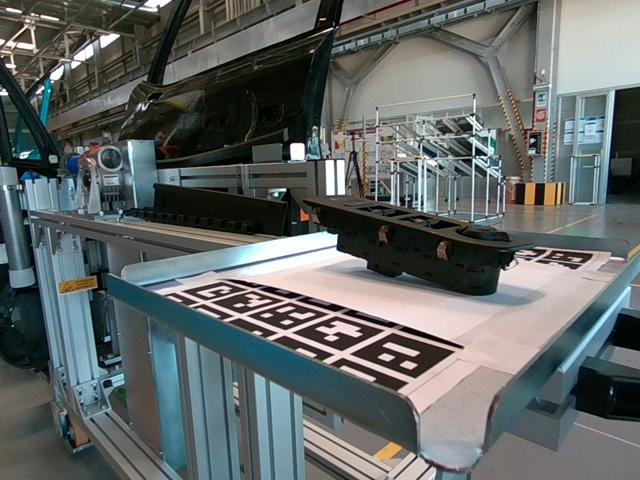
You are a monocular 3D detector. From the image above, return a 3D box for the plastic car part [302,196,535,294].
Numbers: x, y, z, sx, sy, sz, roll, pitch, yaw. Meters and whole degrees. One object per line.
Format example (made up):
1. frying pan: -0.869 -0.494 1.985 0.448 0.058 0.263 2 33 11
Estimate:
1. plastic car part: 0.073 0.001 0.376 0.204 0.067 0.066 12 9 41
